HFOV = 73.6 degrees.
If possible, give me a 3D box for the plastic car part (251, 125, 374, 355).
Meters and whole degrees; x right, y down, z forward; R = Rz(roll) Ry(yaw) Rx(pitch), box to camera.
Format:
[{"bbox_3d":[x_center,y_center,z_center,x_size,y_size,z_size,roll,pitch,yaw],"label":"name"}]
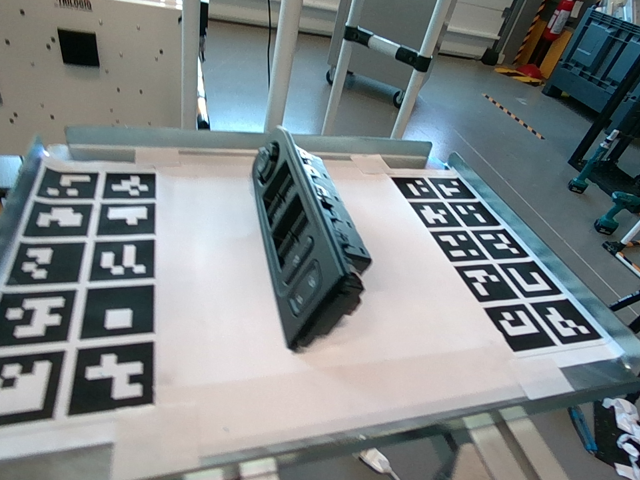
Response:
[{"bbox_3d":[-0.008,-0.018,0.309,0.067,0.066,0.203,8,37,-29],"label":"plastic car part"}]
